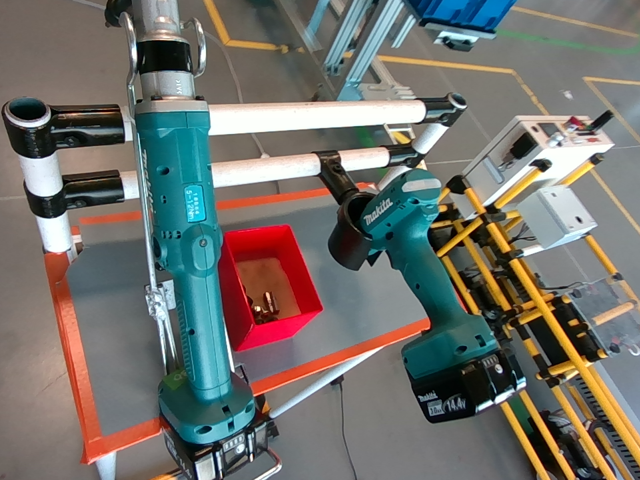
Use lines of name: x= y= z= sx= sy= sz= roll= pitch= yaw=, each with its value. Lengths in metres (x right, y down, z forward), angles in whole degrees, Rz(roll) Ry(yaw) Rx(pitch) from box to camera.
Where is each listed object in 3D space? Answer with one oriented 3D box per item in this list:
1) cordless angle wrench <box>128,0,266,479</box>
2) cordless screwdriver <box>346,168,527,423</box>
cordless angle wrench: x=-0.113 y=0.002 z=0.353 sx=0.074 sy=0.423 sz=0.098 roll=-16 pitch=20 yaw=-42
cordless screwdriver: x=0.105 y=0.063 z=0.466 sx=0.074 sy=0.248 sz=0.160 roll=-11 pitch=-16 yaw=-29
